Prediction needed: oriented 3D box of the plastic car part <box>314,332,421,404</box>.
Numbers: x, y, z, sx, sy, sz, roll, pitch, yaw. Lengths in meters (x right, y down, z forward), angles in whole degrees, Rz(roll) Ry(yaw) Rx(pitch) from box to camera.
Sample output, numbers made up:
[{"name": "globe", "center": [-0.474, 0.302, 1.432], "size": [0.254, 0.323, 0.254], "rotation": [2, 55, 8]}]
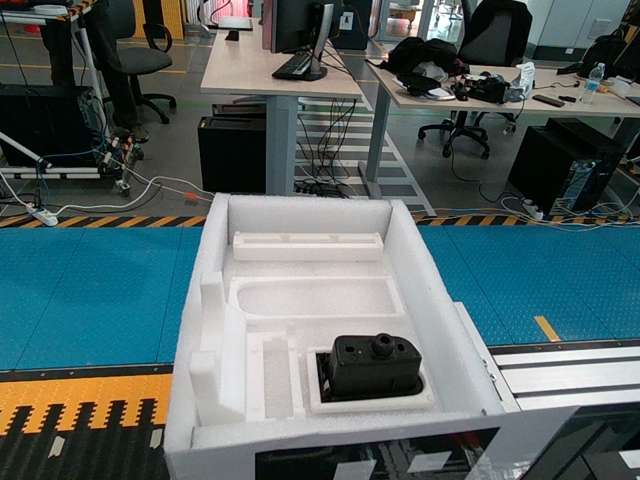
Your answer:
[{"name": "plastic car part", "center": [0.056, 0.131, 0.460], "size": [0.116, 0.071, 0.066], "rotation": [-2, 38, -6]}]
